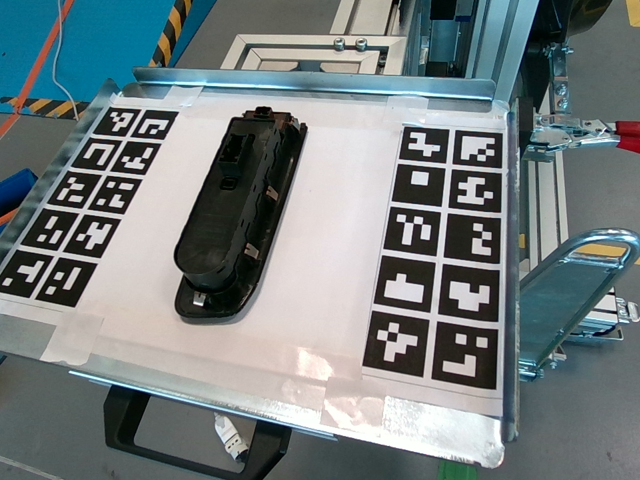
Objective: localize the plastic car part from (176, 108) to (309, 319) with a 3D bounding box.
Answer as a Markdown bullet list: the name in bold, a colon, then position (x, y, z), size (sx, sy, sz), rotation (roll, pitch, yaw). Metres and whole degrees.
- **plastic car part**: position (-0.062, -0.036, 0.337), size (0.066, 0.202, 0.067), rotation (9, -26, 7)
